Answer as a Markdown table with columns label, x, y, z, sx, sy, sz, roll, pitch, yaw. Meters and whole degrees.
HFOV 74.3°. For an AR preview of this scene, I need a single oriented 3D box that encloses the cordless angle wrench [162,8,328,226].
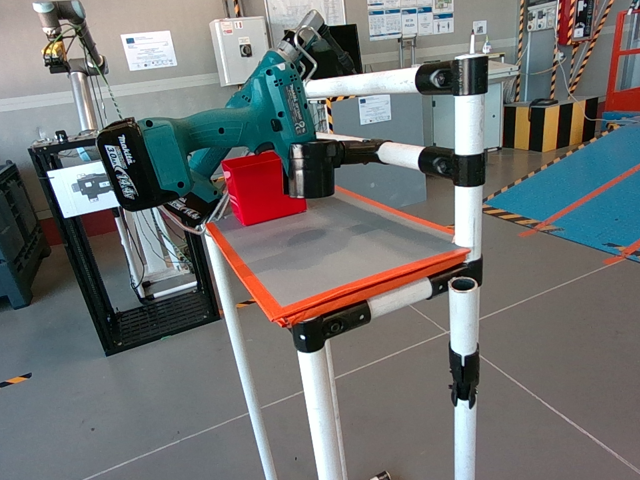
| label | x | y | z | sx | sy | sz | roll | pitch | yaw |
| --- | --- | --- | --- | --- | --- | --- | --- | --- | --- |
| cordless angle wrench | -0.125 | -0.220 | 0.722 | 0.098 | 0.423 | 0.074 | 36 | 0 | -36 |

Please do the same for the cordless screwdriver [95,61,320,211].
| label | x | y | z | sx | sy | sz | roll | pitch | yaw |
| --- | --- | --- | --- | --- | --- | --- | --- | --- | --- |
| cordless screwdriver | -0.119 | -0.100 | 0.506 | 0.248 | 0.159 | 0.074 | -24 | 23 | -16 |
